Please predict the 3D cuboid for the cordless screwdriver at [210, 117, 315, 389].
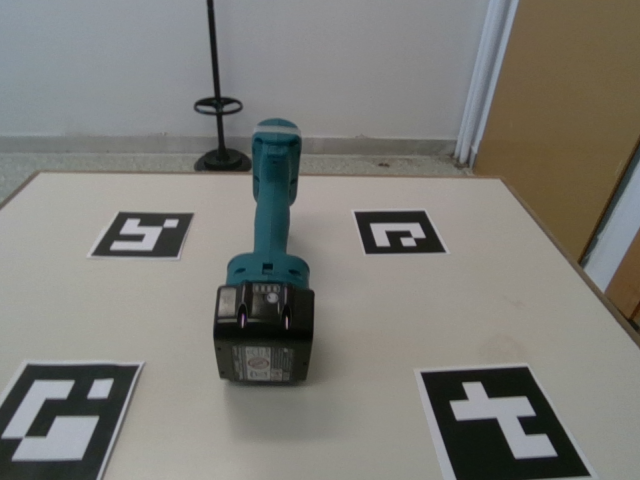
[{"bbox_3d":[-0.049,0.017,0.412,0.074,0.249,0.159,3,-40,-5],"label":"cordless screwdriver"}]
